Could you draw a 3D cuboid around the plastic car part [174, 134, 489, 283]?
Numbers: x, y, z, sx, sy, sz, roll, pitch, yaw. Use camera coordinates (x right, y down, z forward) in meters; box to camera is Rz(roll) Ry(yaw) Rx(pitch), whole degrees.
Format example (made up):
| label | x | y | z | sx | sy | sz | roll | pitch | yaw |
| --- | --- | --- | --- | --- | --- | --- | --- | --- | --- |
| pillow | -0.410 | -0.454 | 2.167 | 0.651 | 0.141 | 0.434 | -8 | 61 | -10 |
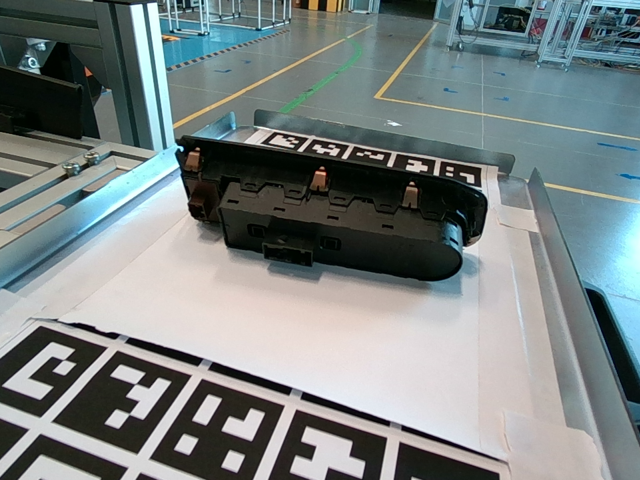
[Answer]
| label | x | y | z | sx | sy | sz | roll | pitch | yaw |
| --- | --- | --- | --- | --- | --- | --- | --- | --- | --- |
| plastic car part | 0.005 | -0.015 | 0.266 | 0.203 | 0.066 | 0.067 | 7 | 44 | 3 |
